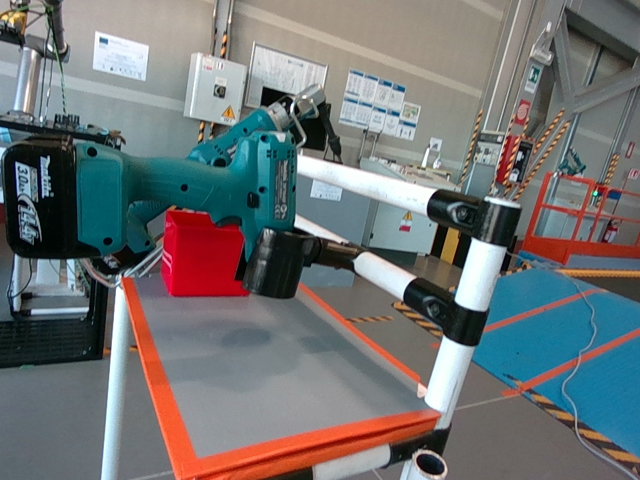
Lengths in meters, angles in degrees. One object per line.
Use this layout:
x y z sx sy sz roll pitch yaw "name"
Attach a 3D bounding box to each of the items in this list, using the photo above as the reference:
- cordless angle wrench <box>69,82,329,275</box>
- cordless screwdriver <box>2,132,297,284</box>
-0.156 -0.115 0.624 0.422 0.098 0.074 -38 40 -12 "cordless angle wrench"
-0.138 -0.021 0.395 0.248 0.159 0.074 -6 18 -28 "cordless screwdriver"
